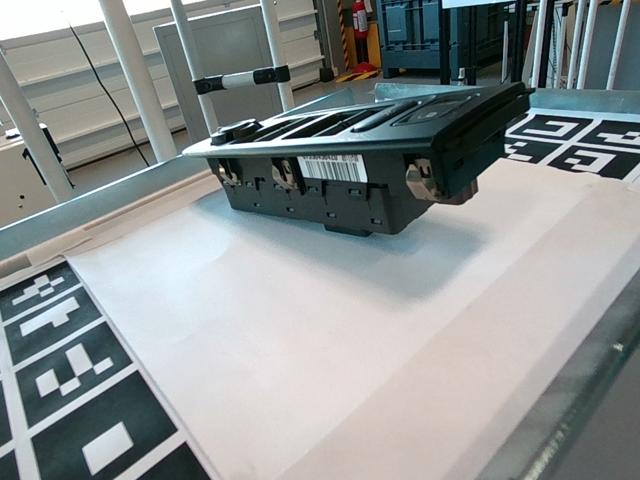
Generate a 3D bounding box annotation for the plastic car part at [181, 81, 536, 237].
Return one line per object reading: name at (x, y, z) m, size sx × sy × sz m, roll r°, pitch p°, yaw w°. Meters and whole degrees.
plastic car part at (-0.002, -0.039, 0.225) m, size 0.204 × 0.067 × 0.066 m, roll 16°, pitch 48°, yaw 45°
